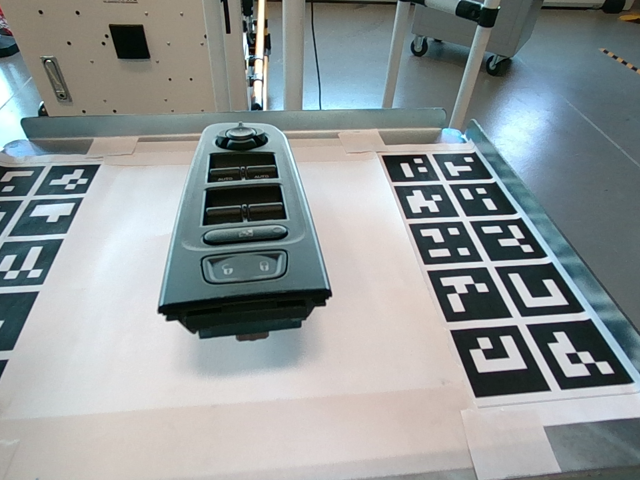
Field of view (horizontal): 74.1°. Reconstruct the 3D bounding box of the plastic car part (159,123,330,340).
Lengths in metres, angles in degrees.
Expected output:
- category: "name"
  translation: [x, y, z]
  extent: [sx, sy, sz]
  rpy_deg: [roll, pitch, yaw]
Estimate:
- category: "plastic car part"
  translation: [-0.041, -0.015, 0.254]
  extent: [0.066, 0.067, 0.203]
  rpy_deg: [-11, 40, -3]
